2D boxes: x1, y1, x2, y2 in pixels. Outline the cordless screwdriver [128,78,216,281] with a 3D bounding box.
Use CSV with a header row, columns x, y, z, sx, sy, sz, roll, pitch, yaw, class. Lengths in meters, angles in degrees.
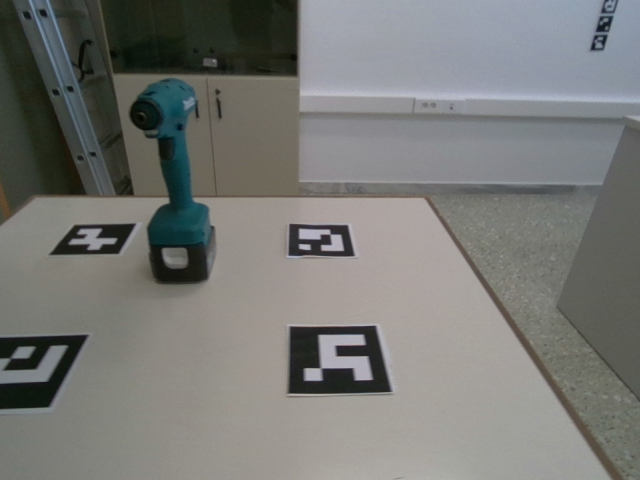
x,y,z,sx,sy,sz,roll,pitch,yaw,class
-0.181,-0.062,0.525,0.074,0.249,0.159,0,25,-3,cordless screwdriver
